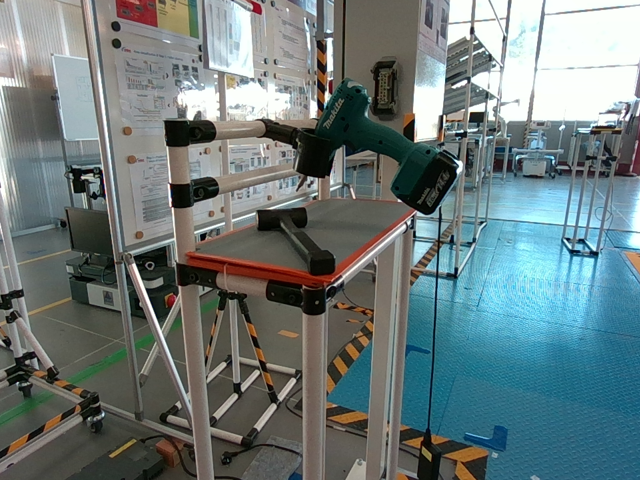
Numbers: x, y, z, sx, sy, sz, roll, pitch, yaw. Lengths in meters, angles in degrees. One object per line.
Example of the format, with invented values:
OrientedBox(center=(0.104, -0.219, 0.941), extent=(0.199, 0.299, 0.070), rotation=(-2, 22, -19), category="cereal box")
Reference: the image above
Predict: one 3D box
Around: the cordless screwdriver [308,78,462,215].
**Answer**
OrientedBox(center=(0.095, -0.131, 0.699), extent=(0.248, 0.159, 0.074), rotation=(39, 29, 11), category="cordless screwdriver")
